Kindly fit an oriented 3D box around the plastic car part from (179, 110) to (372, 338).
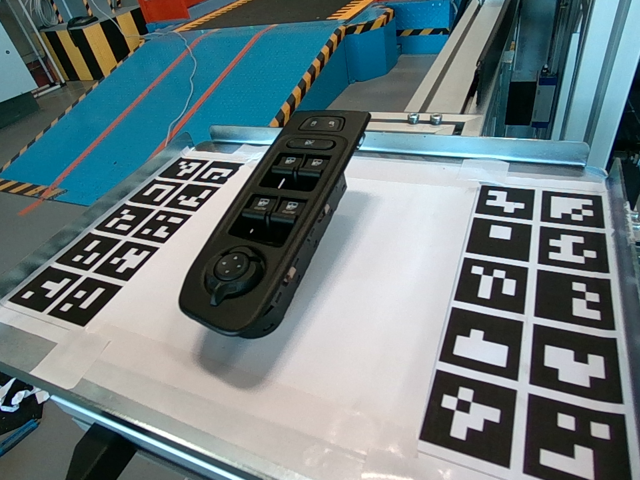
[{"bbox_3d":[-0.024,-0.015,0.295,0.066,0.067,0.202,14,49,17],"label":"plastic car part"}]
